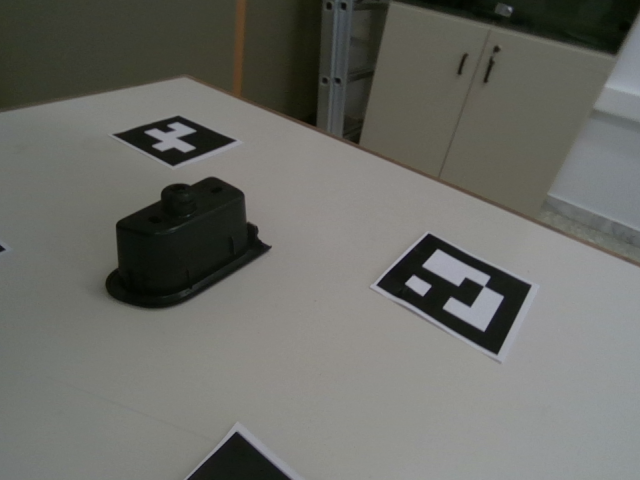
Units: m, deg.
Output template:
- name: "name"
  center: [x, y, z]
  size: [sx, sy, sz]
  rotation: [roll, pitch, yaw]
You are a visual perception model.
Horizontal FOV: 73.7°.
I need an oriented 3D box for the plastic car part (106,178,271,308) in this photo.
- name: "plastic car part"
  center: [-0.095, -0.007, 0.308]
  size: [0.066, 0.071, 0.115]
  rotation: [27, 37, 24]
